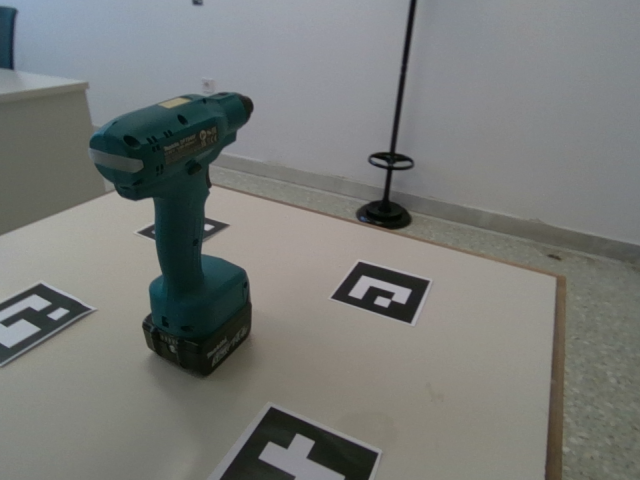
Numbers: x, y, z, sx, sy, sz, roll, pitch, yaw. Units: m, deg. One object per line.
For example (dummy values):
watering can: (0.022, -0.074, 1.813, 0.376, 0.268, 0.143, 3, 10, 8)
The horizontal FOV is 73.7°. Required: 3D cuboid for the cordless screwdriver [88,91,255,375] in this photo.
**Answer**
cordless screwdriver: (-0.108, -0.008, 0.401, 0.075, 0.249, 0.158, 17, 36, 22)
